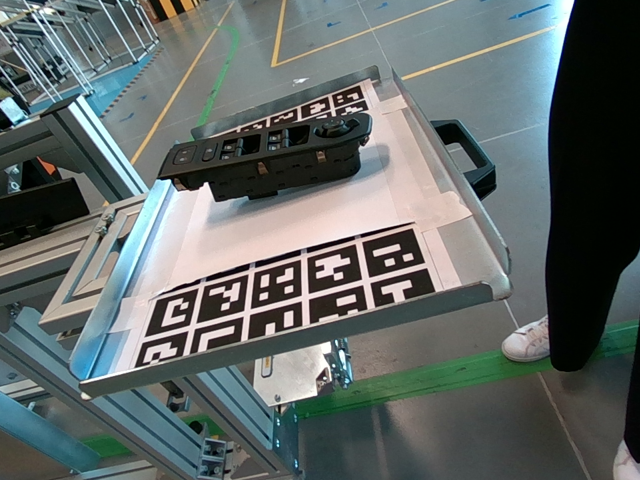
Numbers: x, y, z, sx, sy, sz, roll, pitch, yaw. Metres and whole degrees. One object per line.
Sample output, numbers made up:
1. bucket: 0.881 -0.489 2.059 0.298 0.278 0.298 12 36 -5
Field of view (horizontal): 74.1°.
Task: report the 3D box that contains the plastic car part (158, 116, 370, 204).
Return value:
1. plastic car part: -0.047 -0.073 0.413 0.203 0.067 0.066 -14 30 7
